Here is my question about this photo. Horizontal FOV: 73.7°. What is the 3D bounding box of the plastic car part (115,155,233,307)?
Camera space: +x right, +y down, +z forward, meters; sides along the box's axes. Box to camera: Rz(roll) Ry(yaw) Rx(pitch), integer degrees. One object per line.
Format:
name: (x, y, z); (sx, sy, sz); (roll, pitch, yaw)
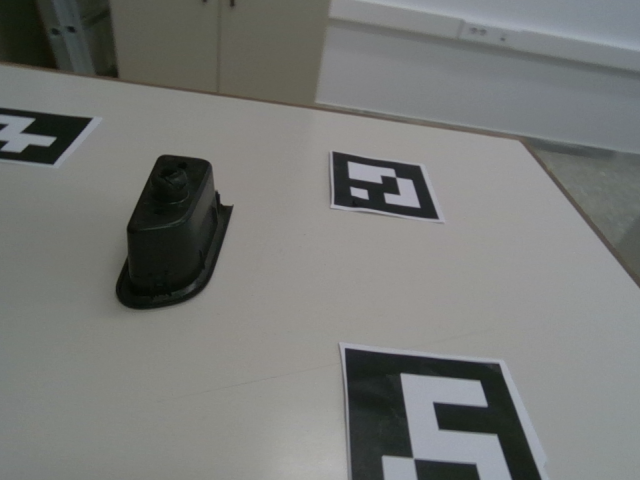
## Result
plastic car part: (-0.100, -0.018, 0.294); (0.066, 0.071, 0.116); (6, 36, -6)
